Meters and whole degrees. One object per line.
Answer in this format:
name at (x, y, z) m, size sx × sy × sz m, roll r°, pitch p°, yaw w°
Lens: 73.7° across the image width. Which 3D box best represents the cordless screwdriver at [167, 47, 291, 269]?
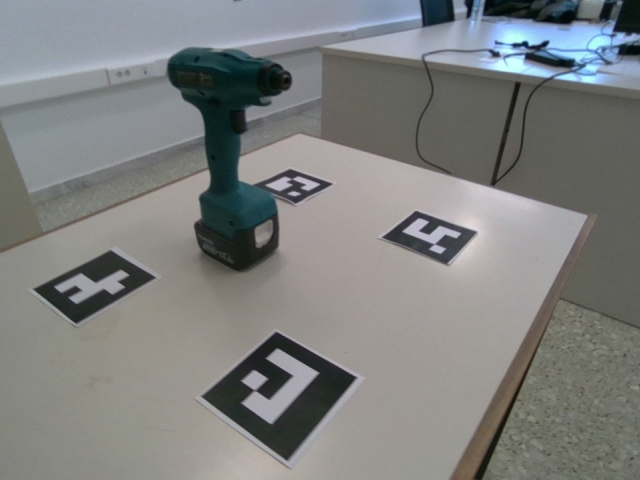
cordless screwdriver at (-0.090, -0.086, 0.492) m, size 0.161 × 0.248 × 0.074 m, roll 20°, pitch 37°, yaw 34°
